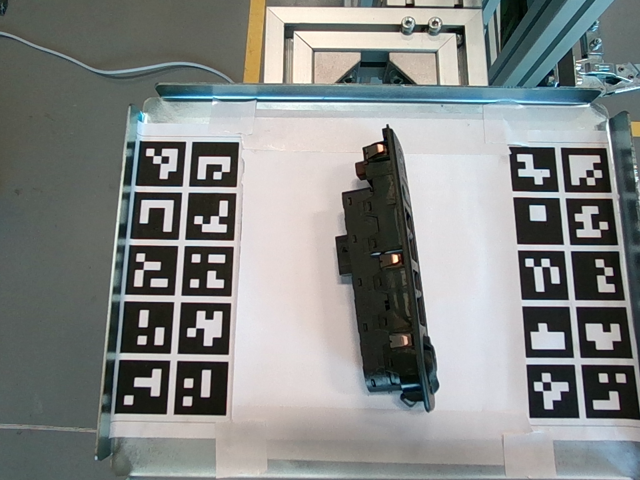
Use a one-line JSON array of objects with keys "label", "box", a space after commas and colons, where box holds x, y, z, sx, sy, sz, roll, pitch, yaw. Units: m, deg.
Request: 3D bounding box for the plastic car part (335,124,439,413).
[{"label": "plastic car part", "box": [0.048, 0.025, 0.315, 0.067, 0.202, 0.066, -12, -9, 10]}]
